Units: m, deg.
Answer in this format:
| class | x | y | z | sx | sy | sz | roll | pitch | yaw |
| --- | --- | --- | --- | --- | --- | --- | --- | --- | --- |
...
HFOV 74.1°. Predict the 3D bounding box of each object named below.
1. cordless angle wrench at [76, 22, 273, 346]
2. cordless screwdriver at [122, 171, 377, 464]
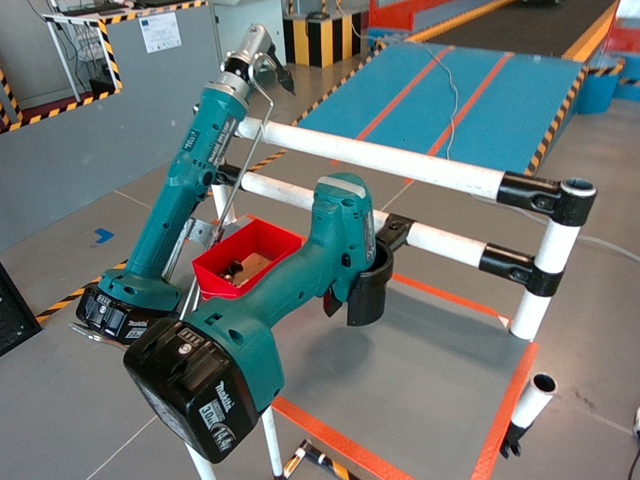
| class | x | y | z | sx | sy | sz | roll | pitch | yaw |
| --- | --- | --- | --- | --- | --- | --- | --- | --- | --- |
| cordless angle wrench | -0.157 | -0.081 | 0.525 | 0.074 | 0.422 | 0.098 | 21 | -6 | 27 |
| cordless screwdriver | -0.030 | 0.067 | 0.372 | 0.074 | 0.159 | 0.248 | 22 | 52 | 32 |
